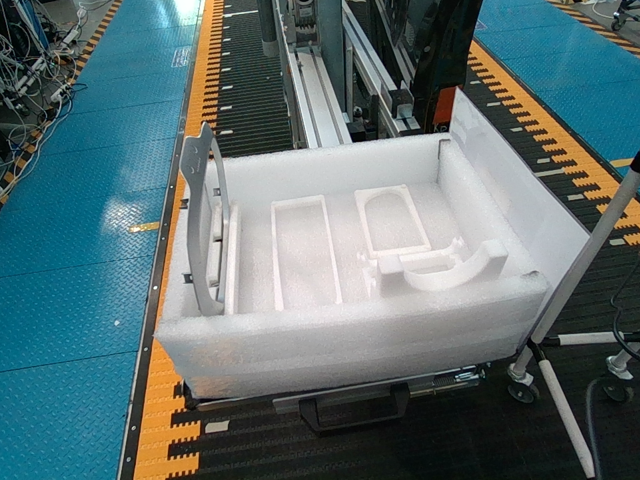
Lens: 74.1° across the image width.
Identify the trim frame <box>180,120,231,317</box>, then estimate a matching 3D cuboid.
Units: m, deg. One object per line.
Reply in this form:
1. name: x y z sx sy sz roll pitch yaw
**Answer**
1. trim frame: -0.128 -0.026 0.490 0.027 0.248 0.184 -2 -41 -3
